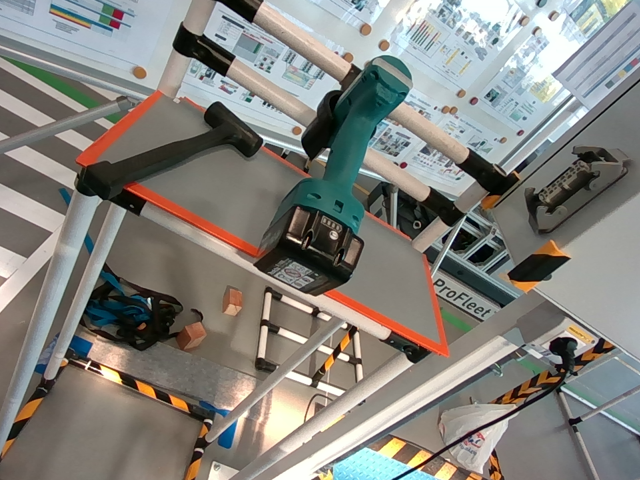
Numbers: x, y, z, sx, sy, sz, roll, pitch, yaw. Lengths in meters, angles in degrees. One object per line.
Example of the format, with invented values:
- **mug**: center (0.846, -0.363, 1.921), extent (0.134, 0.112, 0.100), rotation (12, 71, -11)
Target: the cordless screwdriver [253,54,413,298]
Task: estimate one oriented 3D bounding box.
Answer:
- **cordless screwdriver**: center (0.011, -0.064, 0.453), extent (0.074, 0.248, 0.159), rotation (28, -24, -14)
